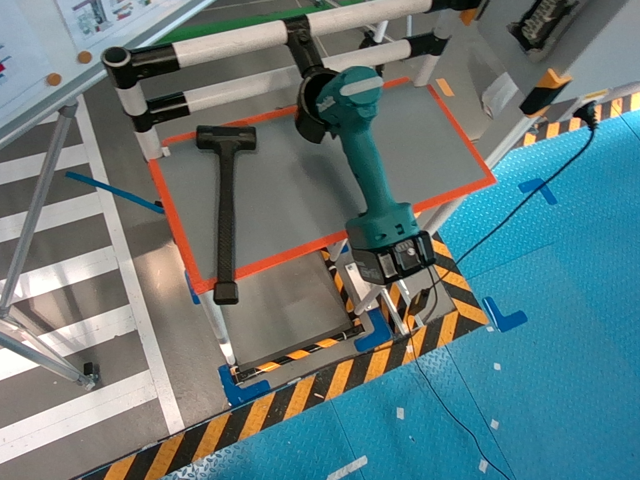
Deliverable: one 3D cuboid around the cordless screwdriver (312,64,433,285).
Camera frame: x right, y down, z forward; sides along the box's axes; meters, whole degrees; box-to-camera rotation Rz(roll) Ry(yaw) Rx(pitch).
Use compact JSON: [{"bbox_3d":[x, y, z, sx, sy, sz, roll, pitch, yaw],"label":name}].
[{"bbox_3d":[0.048,-0.075,0.530,0.074,0.248,0.160,-20,11,-15],"label":"cordless screwdriver"}]
